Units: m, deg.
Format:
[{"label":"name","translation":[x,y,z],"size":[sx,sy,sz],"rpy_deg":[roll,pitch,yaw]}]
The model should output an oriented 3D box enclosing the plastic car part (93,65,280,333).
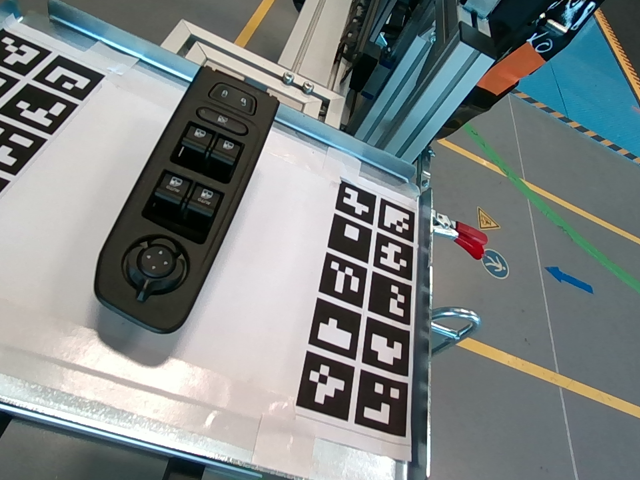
[{"label":"plastic car part","translation":[-0.092,-0.031,0.299],"size":[0.066,0.202,0.067],"rpy_deg":[26,-36,-18]}]
